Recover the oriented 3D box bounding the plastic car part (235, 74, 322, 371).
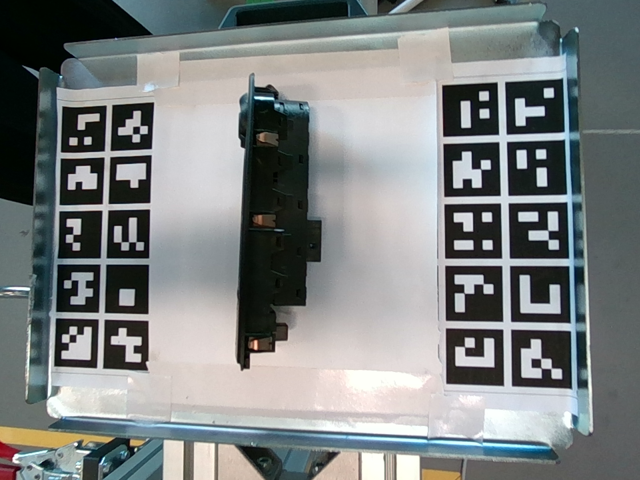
[{"bbox_3d":[-0.032,-0.018,0.302,0.067,0.202,0.066,-3,-3,2],"label":"plastic car part"}]
